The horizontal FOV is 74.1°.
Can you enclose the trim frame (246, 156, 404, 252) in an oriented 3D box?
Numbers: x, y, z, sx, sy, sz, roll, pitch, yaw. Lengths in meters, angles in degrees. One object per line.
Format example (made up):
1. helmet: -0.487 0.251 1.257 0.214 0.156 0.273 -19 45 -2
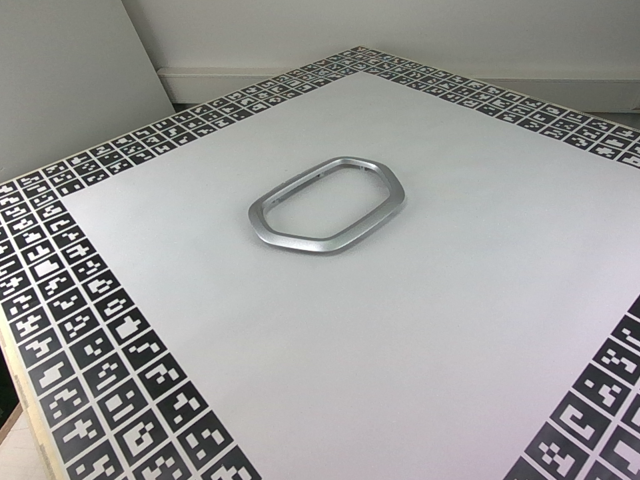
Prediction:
1. trim frame: 0.010 -0.060 0.624 0.185 0.027 0.247 32 55 32
